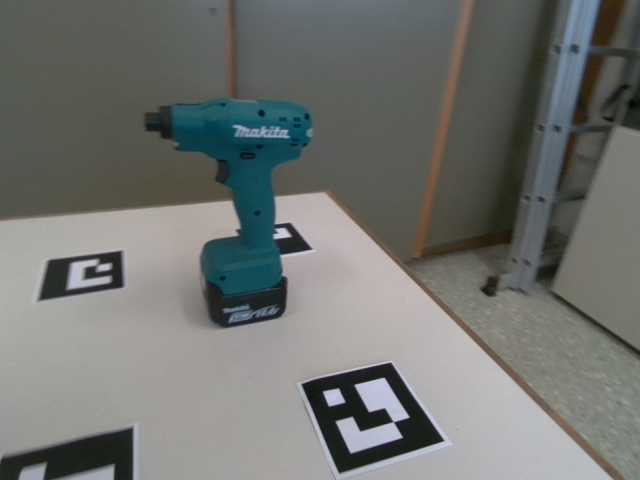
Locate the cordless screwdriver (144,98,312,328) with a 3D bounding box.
[{"bbox_3d":[-0.101,-0.025,0.465,0.158,0.249,0.075,-3,28,-21],"label":"cordless screwdriver"}]
